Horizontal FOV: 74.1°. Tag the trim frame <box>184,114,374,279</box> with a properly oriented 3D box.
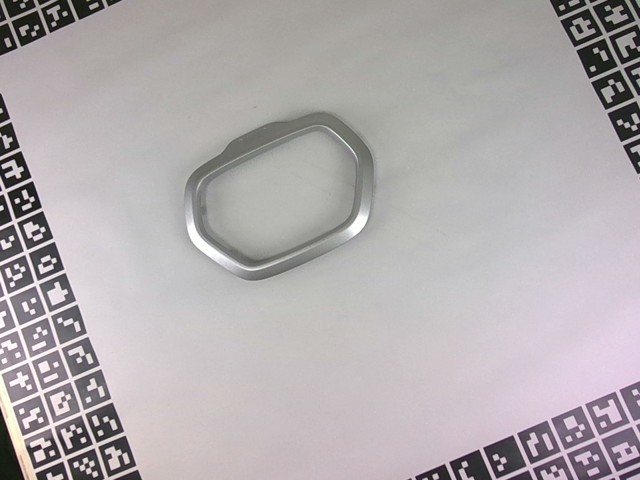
[{"bbox_3d":[-0.049,-0.060,0.530,0.248,0.184,0.027,-28,-8,-3],"label":"trim frame"}]
